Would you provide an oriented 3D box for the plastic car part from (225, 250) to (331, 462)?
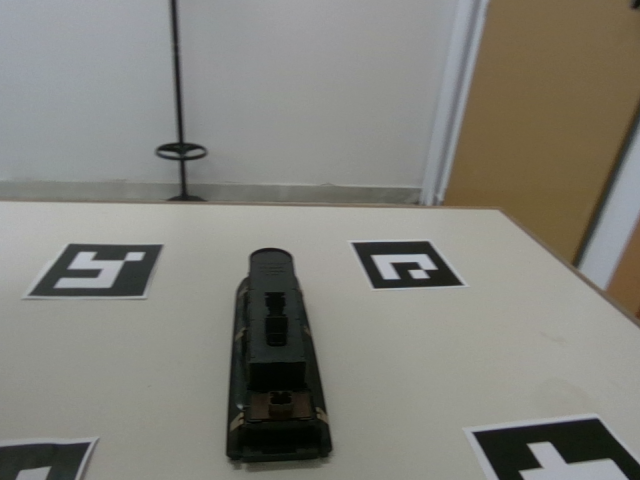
[{"bbox_3d":[-0.040,0.068,0.341,0.066,0.067,0.203,-5,26,-7],"label":"plastic car part"}]
